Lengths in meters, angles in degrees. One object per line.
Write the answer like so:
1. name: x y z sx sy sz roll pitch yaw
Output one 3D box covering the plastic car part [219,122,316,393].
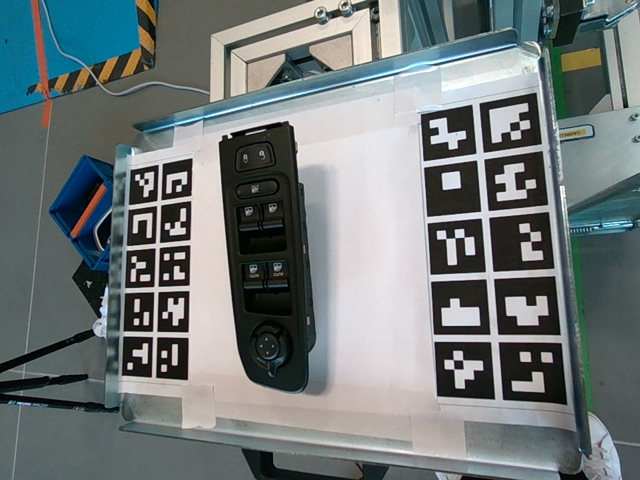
1. plastic car part: -0.037 0.016 0.346 0.066 0.202 0.067 -5 -5 15
